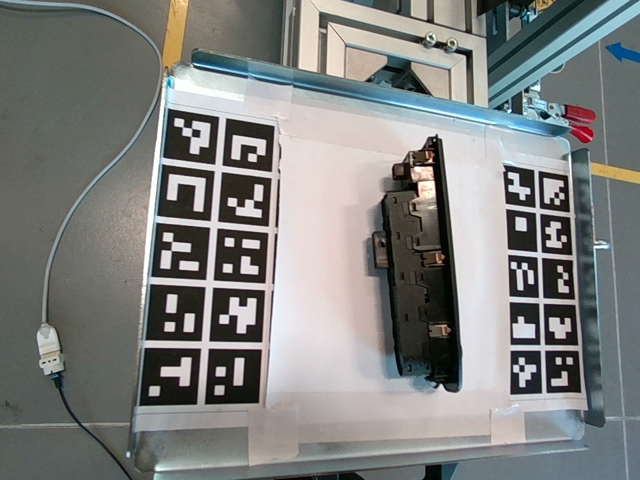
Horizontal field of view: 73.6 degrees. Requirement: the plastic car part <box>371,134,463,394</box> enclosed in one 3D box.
[{"bbox_3d":[0.078,0.024,0.345,0.067,0.202,0.066,-8,-6,-6],"label":"plastic car part"}]
